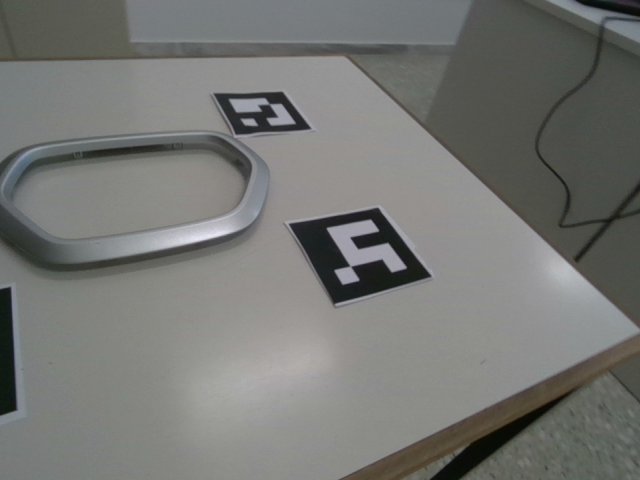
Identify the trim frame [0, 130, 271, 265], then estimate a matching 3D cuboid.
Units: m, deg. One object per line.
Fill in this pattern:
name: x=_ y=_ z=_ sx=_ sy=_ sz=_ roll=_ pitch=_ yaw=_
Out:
trim frame: x=-0.164 y=-0.053 z=0.394 sx=0.246 sy=0.185 sz=0.027 roll=-14 pitch=-38 yaw=-25
